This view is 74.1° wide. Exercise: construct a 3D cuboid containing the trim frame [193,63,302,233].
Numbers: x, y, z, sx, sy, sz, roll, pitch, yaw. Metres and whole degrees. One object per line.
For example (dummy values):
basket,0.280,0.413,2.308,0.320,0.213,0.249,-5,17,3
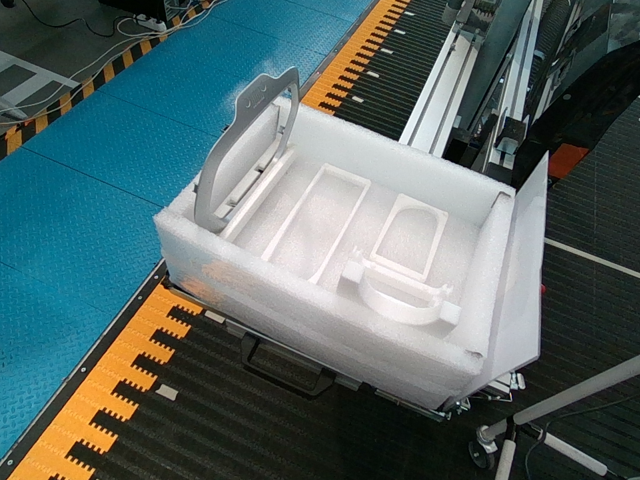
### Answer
trim frame,-0.082,-0.112,0.520,0.027,0.247,0.185,29,-33,6
